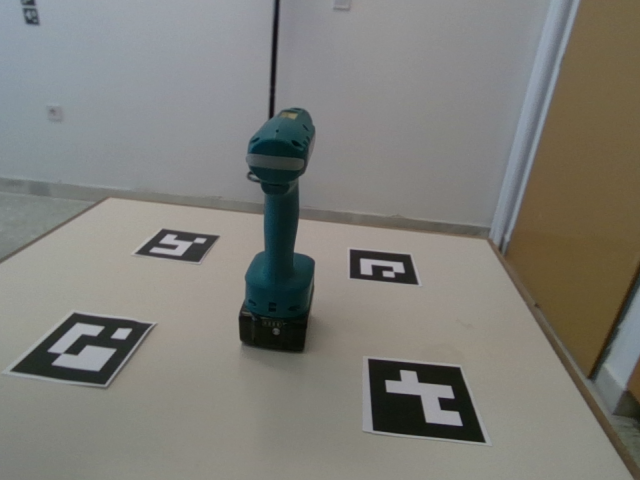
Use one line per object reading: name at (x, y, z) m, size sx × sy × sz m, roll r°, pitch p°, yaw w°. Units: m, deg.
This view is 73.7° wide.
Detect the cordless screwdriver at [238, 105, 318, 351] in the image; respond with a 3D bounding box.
cordless screwdriver at (-0.036, -0.015, 0.462) m, size 0.074 × 0.249 × 0.159 m, roll 7°, pitch 29°, yaw 4°
